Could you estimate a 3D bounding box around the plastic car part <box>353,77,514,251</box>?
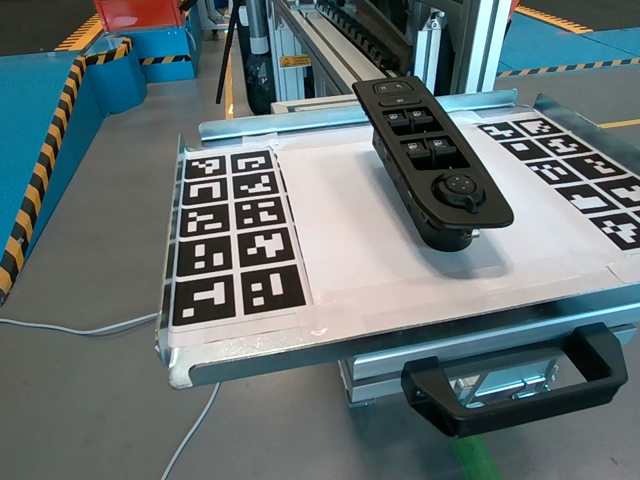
[{"bbox_3d":[0.080,-0.065,0.355,0.066,0.067,0.203,-4,43,-14],"label":"plastic car part"}]
